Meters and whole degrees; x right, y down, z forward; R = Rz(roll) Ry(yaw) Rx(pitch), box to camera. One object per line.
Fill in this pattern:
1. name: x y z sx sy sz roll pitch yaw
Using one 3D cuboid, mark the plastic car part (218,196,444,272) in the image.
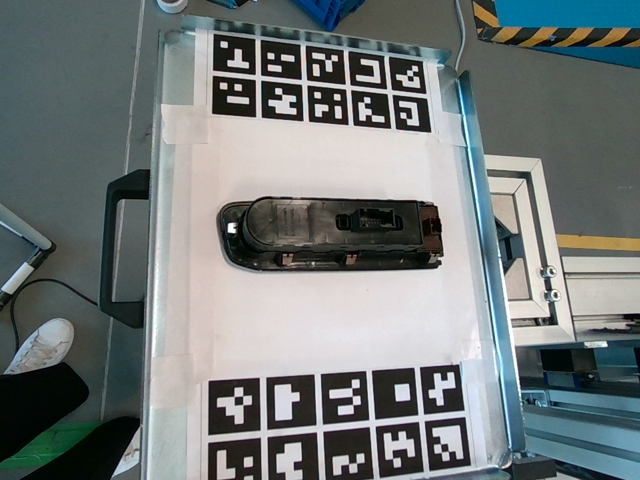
1. plastic car part: 0.019 -0.007 0.358 0.202 0.066 0.067 -1 -7 -12
